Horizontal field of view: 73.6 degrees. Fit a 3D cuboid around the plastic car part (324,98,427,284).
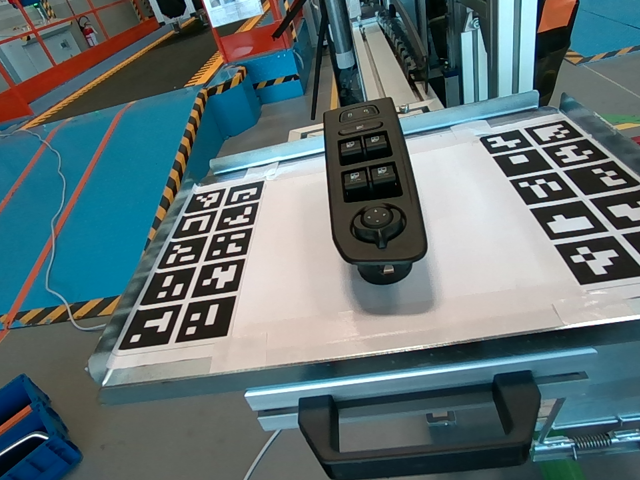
[{"bbox_3d":[0.040,-0.042,0.347,0.066,0.067,0.202,-5,41,3],"label":"plastic car part"}]
